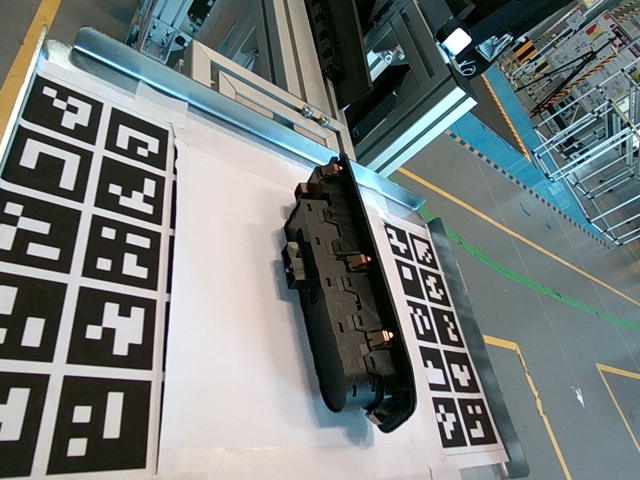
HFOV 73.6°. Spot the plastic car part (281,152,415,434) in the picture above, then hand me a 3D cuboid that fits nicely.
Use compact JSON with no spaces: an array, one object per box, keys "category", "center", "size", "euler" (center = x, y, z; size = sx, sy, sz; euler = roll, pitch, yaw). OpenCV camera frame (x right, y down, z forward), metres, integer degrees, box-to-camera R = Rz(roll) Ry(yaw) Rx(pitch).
[{"category":"plastic car part","center":[0.012,0.032,0.304],"size":[0.067,0.203,0.067],"euler":[-2,-31,-30]}]
